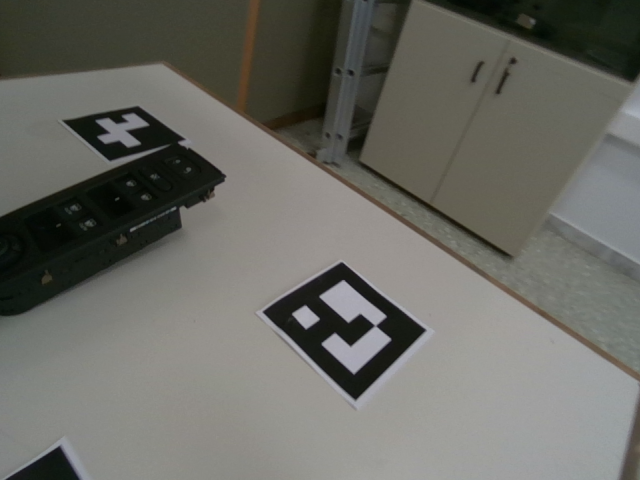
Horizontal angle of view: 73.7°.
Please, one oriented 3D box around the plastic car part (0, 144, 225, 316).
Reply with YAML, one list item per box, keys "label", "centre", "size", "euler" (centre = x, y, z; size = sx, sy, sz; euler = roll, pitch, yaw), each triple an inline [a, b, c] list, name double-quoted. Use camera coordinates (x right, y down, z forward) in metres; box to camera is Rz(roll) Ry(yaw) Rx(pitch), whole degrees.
- label: "plastic car part"
  centre: [-0.172, -0.008, 0.324]
  size: [0.201, 0.066, 0.067]
  euler: [-34, -21, -40]
